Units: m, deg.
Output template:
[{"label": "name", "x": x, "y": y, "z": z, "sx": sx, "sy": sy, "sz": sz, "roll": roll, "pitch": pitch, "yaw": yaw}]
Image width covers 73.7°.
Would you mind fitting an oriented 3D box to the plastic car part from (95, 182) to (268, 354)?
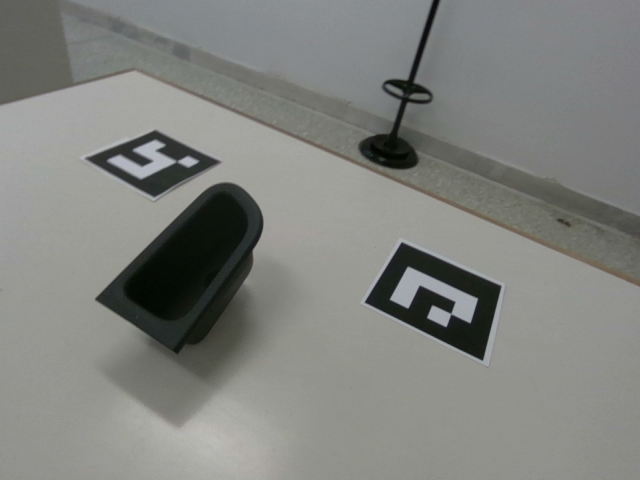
[{"label": "plastic car part", "x": -0.075, "y": 0.025, "z": 0.292, "sx": 0.066, "sy": 0.116, "sz": 0.071, "roll": 25, "pitch": -34, "yaw": 19}]
